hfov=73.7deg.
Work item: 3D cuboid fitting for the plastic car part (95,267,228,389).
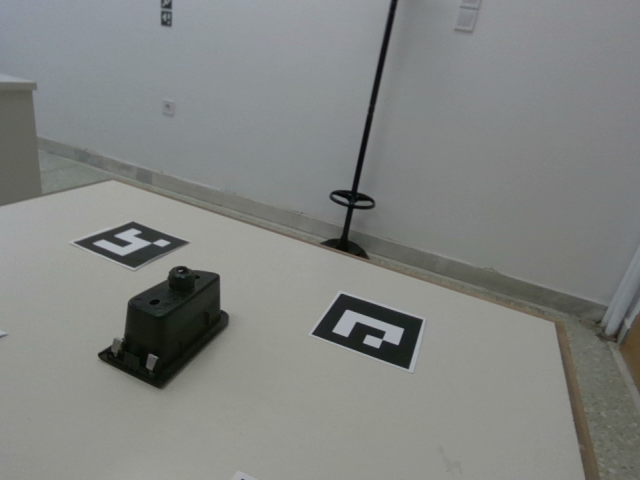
[{"bbox_3d":[-0.129,0.062,0.378,0.066,0.071,0.116,18,28,15],"label":"plastic car part"}]
